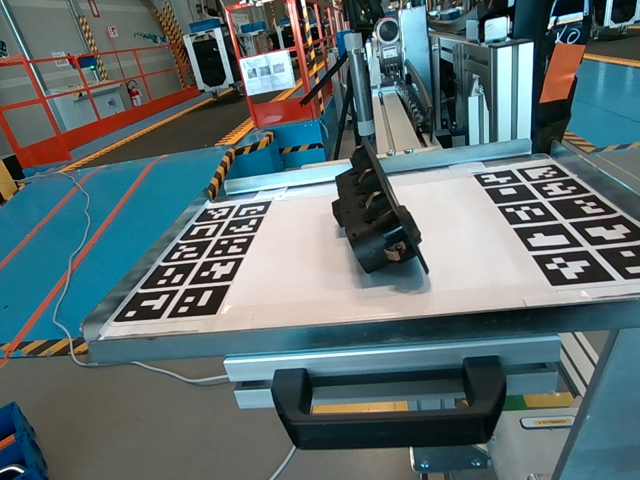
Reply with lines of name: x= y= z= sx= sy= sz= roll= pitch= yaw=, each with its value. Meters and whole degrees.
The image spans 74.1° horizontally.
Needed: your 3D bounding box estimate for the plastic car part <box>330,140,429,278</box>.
plastic car part: x=0.043 y=-0.030 z=0.371 sx=0.067 sy=0.066 sz=0.203 roll=-21 pitch=25 yaw=4
